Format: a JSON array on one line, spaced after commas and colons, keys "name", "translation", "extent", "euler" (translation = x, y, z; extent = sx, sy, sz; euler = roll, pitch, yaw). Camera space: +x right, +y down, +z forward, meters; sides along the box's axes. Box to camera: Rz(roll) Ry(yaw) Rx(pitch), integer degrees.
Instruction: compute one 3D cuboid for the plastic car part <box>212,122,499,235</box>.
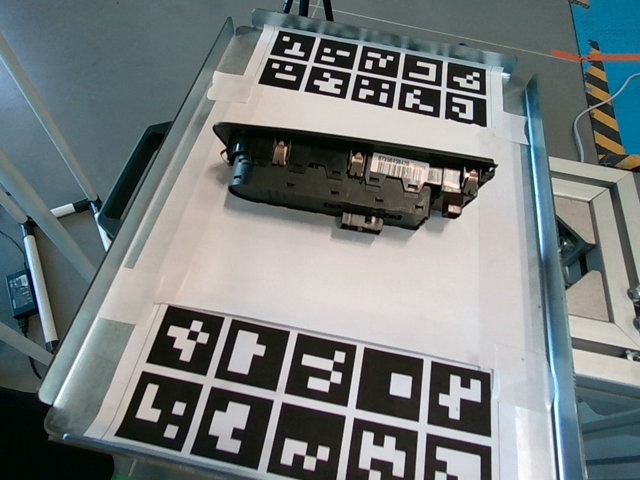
[{"name": "plastic car part", "translation": [0.017, -0.043, 0.321], "extent": [0.203, 0.067, 0.066], "euler": [14, -4, 4]}]
